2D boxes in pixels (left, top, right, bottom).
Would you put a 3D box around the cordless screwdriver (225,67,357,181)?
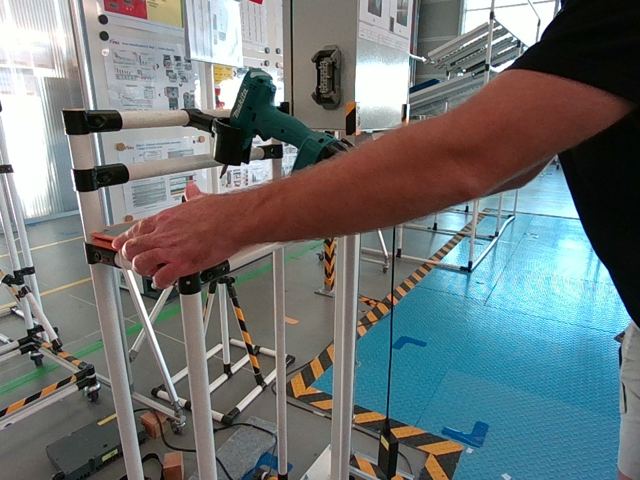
[{"bbox_3d":[-0.057,-0.150,0.702,0.248,0.160,0.074,42,33,15],"label":"cordless screwdriver"}]
